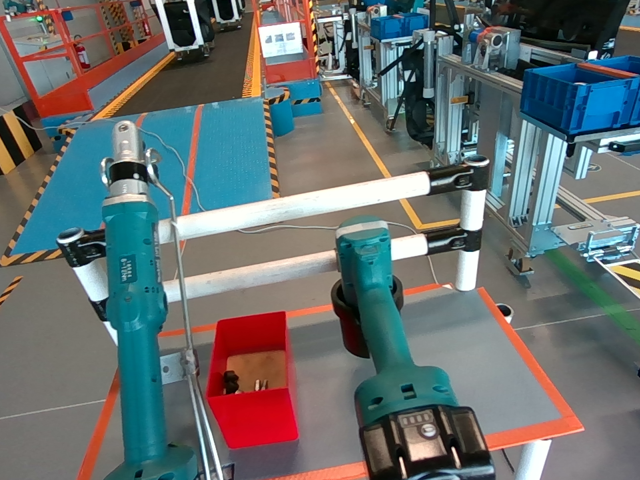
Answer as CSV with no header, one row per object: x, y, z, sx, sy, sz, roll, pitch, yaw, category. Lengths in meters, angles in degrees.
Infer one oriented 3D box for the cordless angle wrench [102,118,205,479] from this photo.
-0.181,0.067,0.426,0.074,0.422,0.098,-10,-14,-4,cordless angle wrench

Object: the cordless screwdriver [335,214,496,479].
0.059,0.109,0.362,0.074,0.159,0.248,-10,40,1,cordless screwdriver
